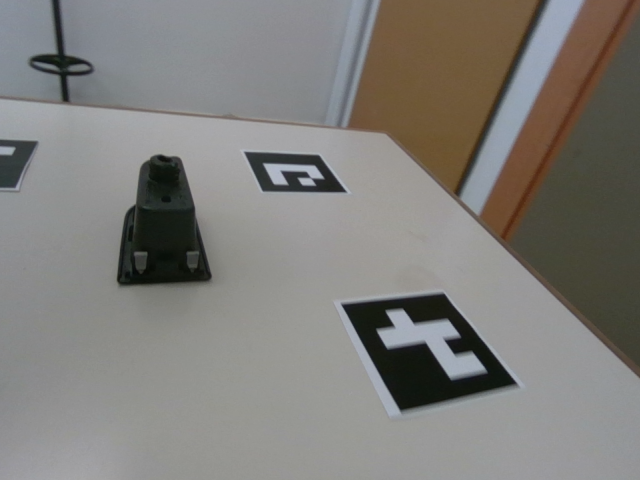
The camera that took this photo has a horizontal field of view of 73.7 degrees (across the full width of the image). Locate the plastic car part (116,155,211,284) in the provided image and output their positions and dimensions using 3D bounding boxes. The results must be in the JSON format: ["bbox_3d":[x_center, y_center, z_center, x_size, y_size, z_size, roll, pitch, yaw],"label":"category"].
[{"bbox_3d":[-0.125,-0.028,0.338,0.065,0.071,0.117,-1,39,-22],"label":"plastic car part"}]
